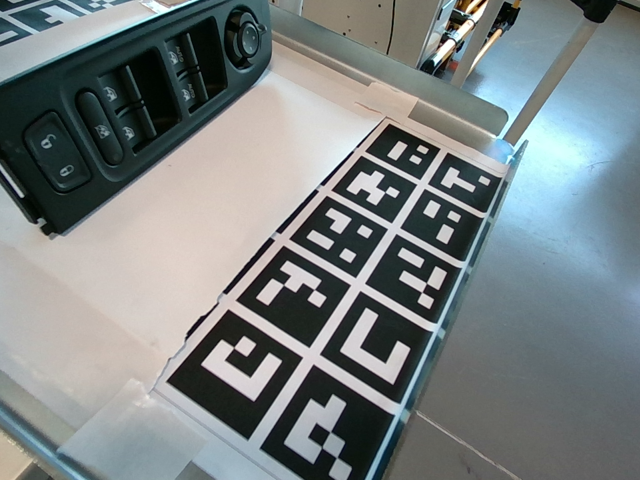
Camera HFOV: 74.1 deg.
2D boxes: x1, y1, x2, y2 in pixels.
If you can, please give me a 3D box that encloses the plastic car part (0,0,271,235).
[{"bbox_3d":[-0.098,-0.091,0.247,0.067,0.066,0.202,13,47,33],"label":"plastic car part"}]
